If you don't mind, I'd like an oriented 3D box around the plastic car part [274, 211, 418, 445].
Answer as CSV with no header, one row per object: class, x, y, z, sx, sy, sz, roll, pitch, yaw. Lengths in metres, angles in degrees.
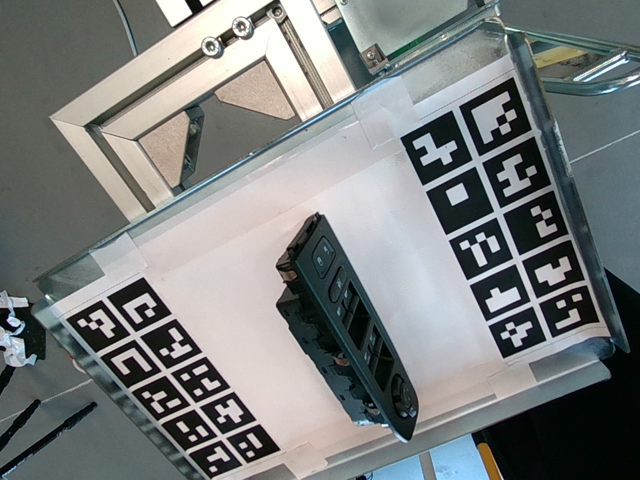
plastic car part,0.018,0.083,0.334,0.067,0.202,0.066,-25,20,22
